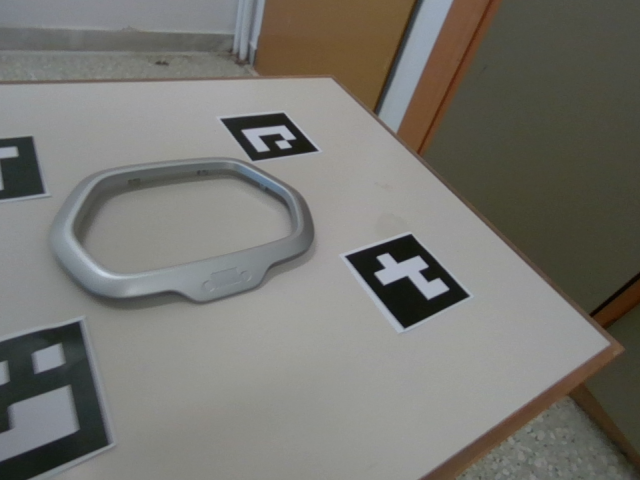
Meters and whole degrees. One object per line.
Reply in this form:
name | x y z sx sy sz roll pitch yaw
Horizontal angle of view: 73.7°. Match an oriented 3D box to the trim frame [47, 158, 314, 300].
trim frame | -0.123 -0.020 0.418 0.246 0.027 0.185 -14 49 -32
